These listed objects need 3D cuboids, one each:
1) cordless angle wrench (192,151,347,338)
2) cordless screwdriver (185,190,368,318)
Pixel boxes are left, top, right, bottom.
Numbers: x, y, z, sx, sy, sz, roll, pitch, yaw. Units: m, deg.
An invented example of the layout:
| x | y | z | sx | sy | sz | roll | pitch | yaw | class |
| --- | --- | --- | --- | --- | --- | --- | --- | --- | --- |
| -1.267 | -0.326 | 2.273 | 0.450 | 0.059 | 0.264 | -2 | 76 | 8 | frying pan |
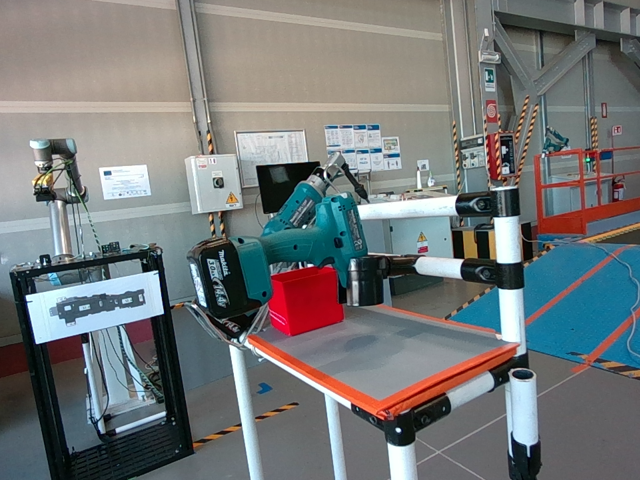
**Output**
| x | y | z | sx | sy | sz | roll | pitch | yaw | class |
| --- | --- | --- | --- | --- | --- | --- | --- | --- | --- |
| -0.075 | -0.015 | 0.812 | 0.098 | 0.422 | 0.074 | 45 | -20 | -28 | cordless angle wrench |
| -0.041 | 0.038 | 0.571 | 0.248 | 0.159 | 0.074 | -20 | 12 | -28 | cordless screwdriver |
